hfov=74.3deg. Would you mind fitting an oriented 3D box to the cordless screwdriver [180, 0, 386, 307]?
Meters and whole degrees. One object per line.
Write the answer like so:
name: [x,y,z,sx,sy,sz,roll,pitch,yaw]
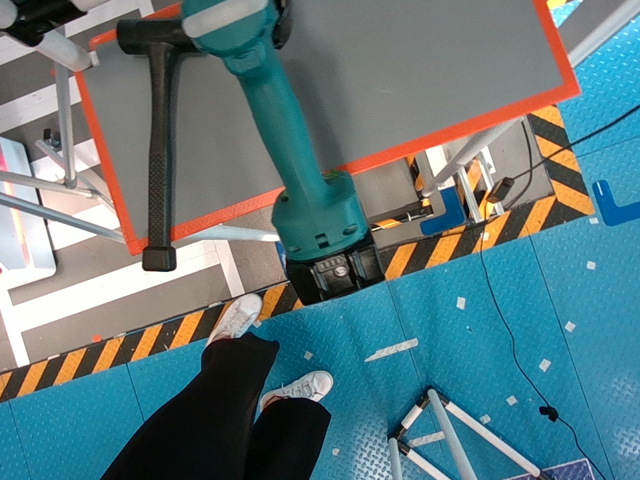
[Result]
cordless screwdriver: [-0.023,-0.079,0.343,0.074,0.249,0.159,-19,29,6]
